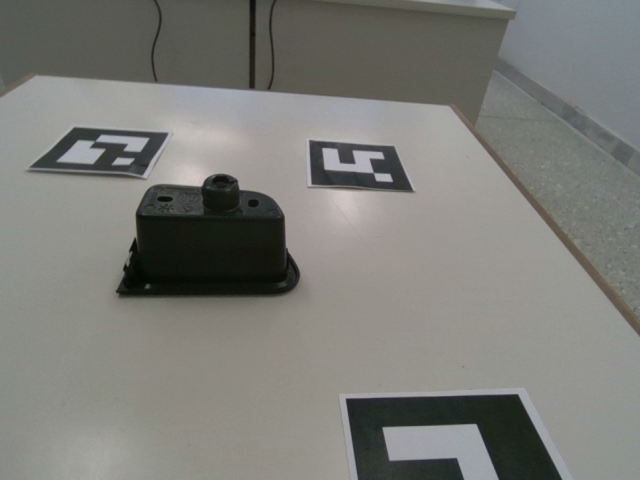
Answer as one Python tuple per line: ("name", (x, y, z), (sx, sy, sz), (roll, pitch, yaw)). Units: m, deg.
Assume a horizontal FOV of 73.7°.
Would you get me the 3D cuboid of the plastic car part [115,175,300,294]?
("plastic car part", (-0.071, -0.008, 0.280), (0.116, 0.071, 0.066), (-1, 38, -4))
